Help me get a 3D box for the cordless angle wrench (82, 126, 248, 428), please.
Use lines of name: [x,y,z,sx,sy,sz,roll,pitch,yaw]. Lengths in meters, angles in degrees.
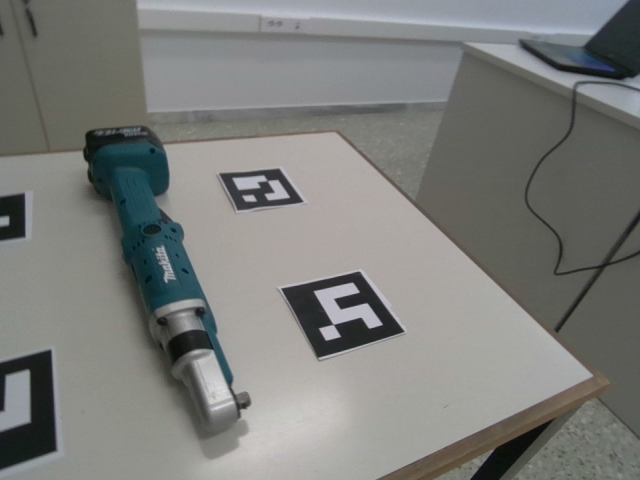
cordless angle wrench: [-0.178,0.009,0.463,0.097,0.074,0.426,-13,46,-27]
